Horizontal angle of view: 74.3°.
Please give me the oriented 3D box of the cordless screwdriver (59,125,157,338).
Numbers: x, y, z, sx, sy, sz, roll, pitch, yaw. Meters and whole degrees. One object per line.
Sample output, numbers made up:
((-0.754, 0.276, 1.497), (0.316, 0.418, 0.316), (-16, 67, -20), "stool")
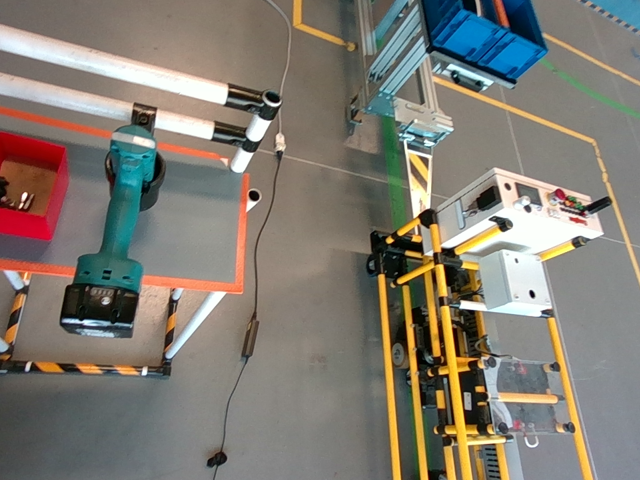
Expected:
((-0.254, -0.004, 0.539), (0.074, 0.248, 0.159), (10, -16, -20), "cordless screwdriver")
